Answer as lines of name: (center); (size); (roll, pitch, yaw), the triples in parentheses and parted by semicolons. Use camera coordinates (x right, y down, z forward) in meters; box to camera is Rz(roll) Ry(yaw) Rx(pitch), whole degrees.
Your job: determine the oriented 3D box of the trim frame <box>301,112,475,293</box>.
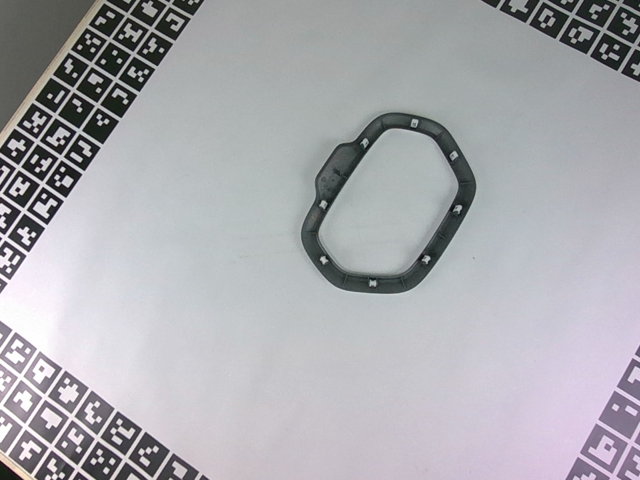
trim frame: (0.084, -0.048, 0.533); (0.184, 0.248, 0.027); (33, -4, 6)
